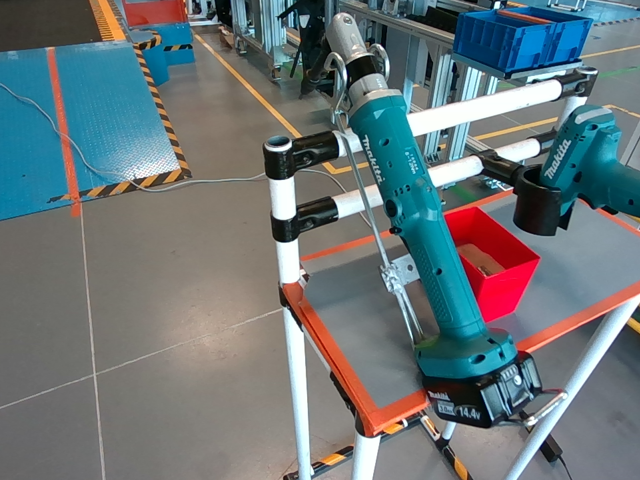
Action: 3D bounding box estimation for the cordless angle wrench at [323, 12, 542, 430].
[{"bbox_3d":[0.089,-0.035,0.423,0.074,0.422,0.098,-18,-5,-28],"label":"cordless angle wrench"}]

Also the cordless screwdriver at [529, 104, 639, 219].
[{"bbox_3d":[0.338,-0.018,0.456,0.074,0.160,0.248,-18,50,-18],"label":"cordless screwdriver"}]
